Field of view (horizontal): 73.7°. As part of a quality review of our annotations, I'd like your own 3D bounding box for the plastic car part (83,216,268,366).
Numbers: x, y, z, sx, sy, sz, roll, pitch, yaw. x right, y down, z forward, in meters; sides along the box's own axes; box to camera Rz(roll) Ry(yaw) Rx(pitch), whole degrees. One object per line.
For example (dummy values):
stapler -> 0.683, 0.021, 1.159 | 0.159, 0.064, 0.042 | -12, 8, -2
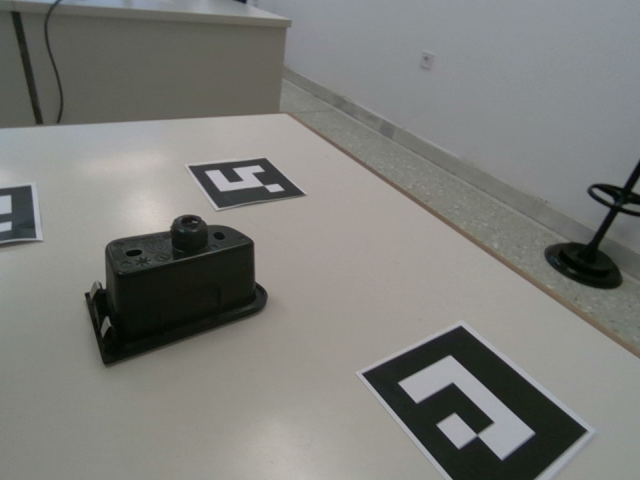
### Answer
plastic car part -> -0.091, 0.020, 0.281 | 0.115, 0.071, 0.066 | -17, 43, -31
